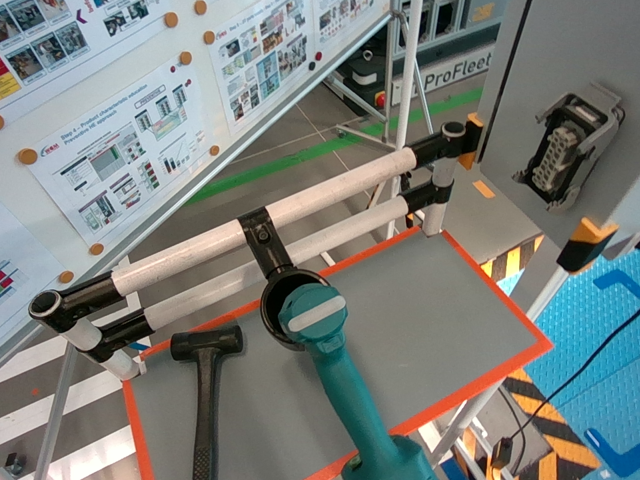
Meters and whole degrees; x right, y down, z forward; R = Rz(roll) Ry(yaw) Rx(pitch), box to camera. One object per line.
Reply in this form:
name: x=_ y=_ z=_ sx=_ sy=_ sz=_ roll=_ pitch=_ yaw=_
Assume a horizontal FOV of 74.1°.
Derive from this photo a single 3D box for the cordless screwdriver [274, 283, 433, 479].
cordless screwdriver: x=0.027 y=0.158 z=0.392 sx=0.074 sy=0.248 sz=0.159 roll=-25 pitch=-6 yaw=-12
